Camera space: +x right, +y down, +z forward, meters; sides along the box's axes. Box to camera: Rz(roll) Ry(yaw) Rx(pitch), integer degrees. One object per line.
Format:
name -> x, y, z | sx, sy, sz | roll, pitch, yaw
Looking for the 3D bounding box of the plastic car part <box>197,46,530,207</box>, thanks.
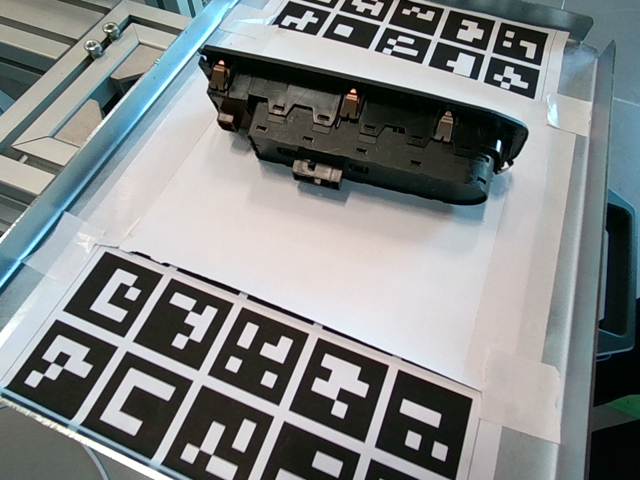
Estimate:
plastic car part -> 0.024, -0.062, 0.259 | 0.203, 0.067, 0.066 | 10, -18, 3
